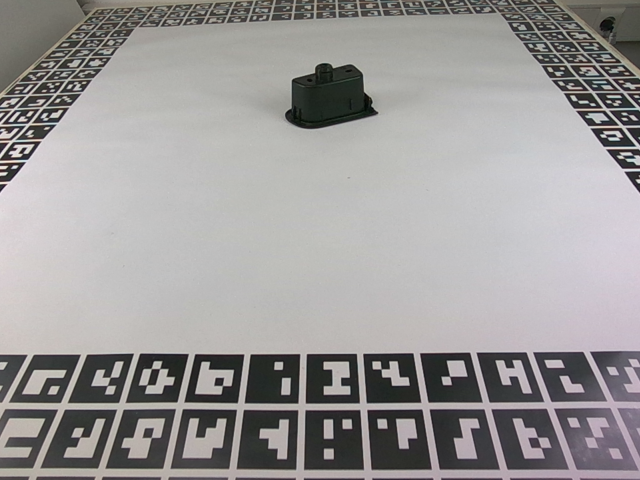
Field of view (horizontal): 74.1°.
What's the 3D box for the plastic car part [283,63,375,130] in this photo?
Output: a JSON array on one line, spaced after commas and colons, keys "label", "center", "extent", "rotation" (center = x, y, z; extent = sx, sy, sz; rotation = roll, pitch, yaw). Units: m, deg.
[{"label": "plastic car part", "center": [0.011, -0.194, 0.555], "extent": [0.116, 0.066, 0.071], "rotation": [-19, -32, -18]}]
